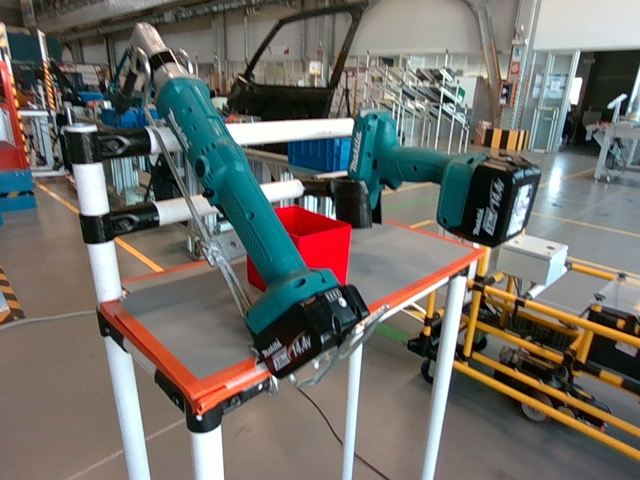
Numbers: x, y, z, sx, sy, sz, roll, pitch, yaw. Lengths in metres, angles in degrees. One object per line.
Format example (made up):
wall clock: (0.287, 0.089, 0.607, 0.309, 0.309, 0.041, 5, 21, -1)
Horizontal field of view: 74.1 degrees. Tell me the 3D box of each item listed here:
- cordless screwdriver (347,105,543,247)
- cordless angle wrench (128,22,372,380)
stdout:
cordless screwdriver: (0.130, -0.064, 0.536, 0.074, 0.159, 0.249, -20, 39, -39)
cordless angle wrench: (-0.102, -0.071, 0.434, 0.074, 0.422, 0.098, -15, -23, -47)
